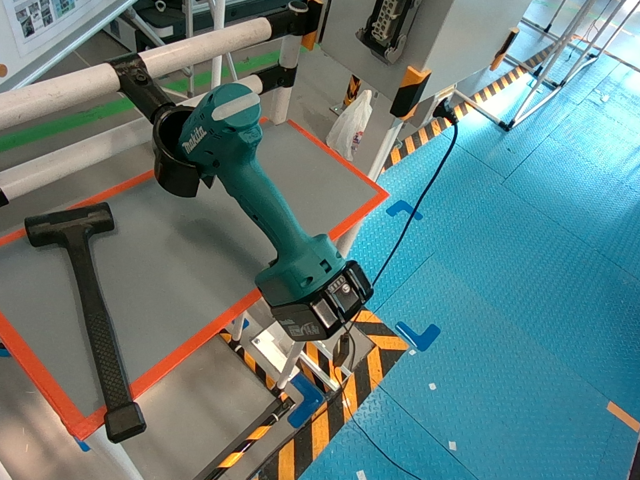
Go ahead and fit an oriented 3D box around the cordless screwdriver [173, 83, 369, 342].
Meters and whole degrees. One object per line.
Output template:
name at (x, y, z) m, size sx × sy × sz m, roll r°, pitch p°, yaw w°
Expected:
cordless screwdriver at (-0.067, -0.016, 0.435) m, size 0.074 × 0.248 × 0.160 m, roll -38°, pitch 12°, yaw -34°
